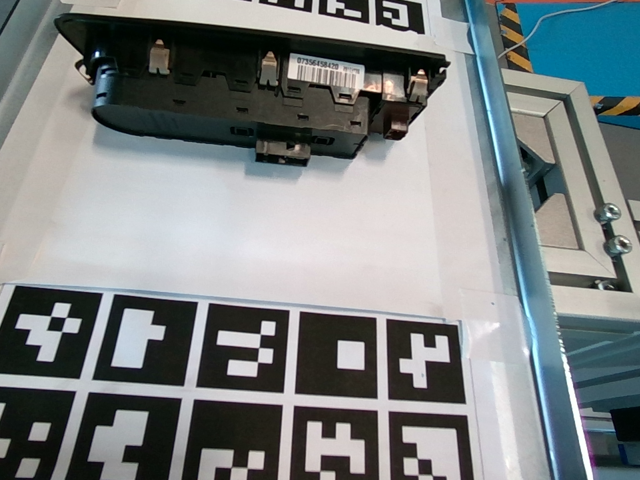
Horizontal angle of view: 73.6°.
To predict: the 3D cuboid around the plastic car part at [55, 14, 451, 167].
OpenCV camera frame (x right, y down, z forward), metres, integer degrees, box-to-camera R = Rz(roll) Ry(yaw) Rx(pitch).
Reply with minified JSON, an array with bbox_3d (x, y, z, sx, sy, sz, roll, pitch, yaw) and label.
[{"bbox_3d":[-0.037,-0.079,0.242,0.203,0.067,0.066,9,-1,-6],"label":"plastic car part"}]
